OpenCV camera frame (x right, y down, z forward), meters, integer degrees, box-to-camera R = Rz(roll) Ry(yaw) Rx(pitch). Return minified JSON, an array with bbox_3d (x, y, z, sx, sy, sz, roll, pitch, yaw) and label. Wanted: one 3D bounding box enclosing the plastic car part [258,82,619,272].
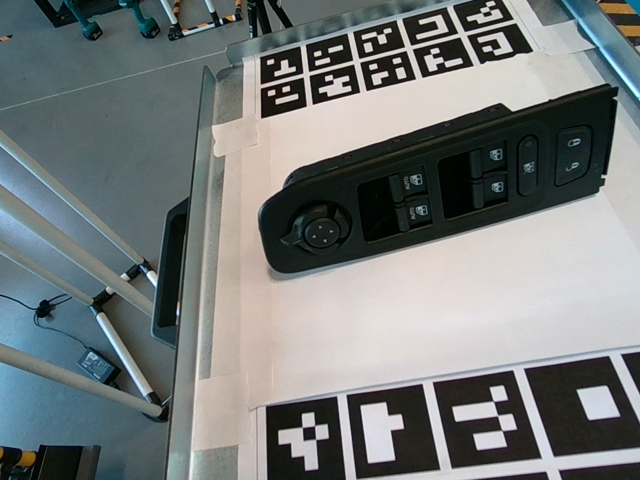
[{"bbox_3d":[0.058,-0.039,0.255,0.203,0.066,0.067,-19,43,2],"label":"plastic car part"}]
